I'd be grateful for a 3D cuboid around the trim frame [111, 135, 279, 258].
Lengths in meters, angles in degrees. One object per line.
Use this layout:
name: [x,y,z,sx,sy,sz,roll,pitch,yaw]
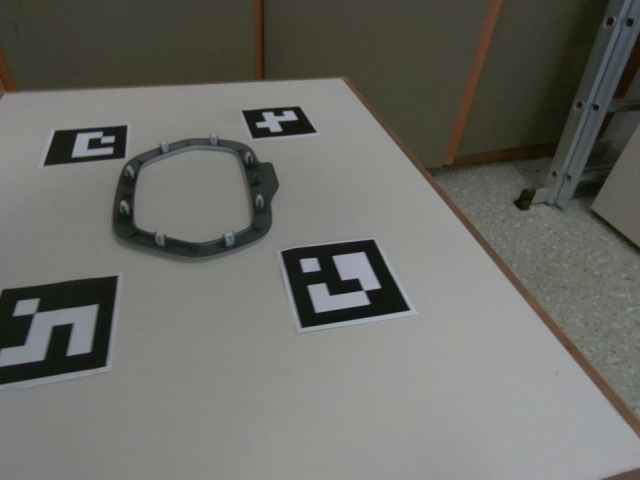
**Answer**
trim frame: [-0.142,-0.063,0.495,0.183,0.027,0.249,-7,39,-13]
